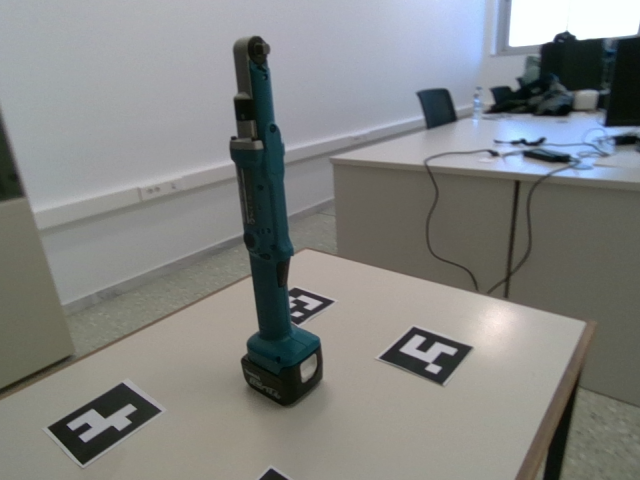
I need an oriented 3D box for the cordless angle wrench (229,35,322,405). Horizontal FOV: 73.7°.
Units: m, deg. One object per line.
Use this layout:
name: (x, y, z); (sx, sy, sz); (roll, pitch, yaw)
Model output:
cordless angle wrench: (-0.062, -0.007, 0.502); (0.099, 0.422, 0.073); (13, 26, 38)
